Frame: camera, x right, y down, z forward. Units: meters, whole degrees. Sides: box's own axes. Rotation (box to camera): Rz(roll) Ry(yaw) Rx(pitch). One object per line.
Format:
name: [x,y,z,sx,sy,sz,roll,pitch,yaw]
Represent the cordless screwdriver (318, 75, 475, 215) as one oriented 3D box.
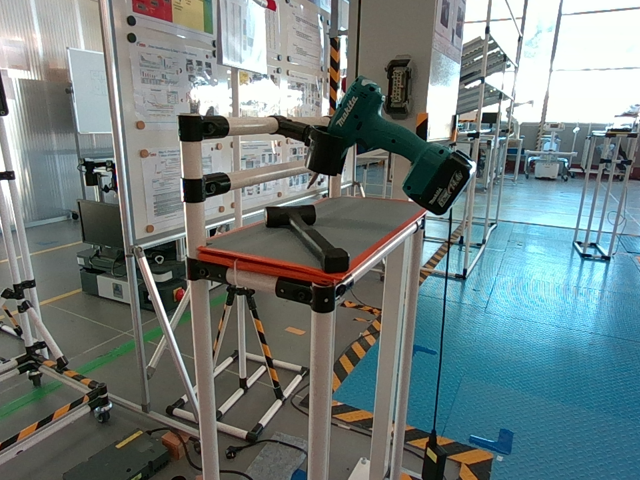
cordless screwdriver: [0.117,-0.133,0.697,0.248,0.159,0.074,40,28,10]
